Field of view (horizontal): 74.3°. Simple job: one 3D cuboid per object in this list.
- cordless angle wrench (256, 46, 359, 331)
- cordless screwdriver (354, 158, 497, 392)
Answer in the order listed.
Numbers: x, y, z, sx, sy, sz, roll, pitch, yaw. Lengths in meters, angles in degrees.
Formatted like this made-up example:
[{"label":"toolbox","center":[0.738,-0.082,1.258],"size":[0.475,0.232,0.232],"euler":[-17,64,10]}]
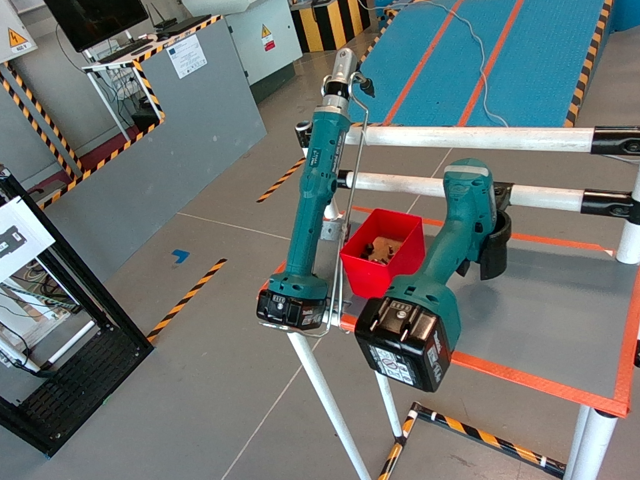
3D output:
[{"label":"cordless angle wrench","center":[-0.001,-0.081,0.632],"size":[0.074,0.423,0.098],"euler":[12,0,28]},{"label":"cordless screwdriver","center":[0.139,0.046,0.476],"size":[0.074,0.248,0.159],"euler":[13,-33,36]}]
